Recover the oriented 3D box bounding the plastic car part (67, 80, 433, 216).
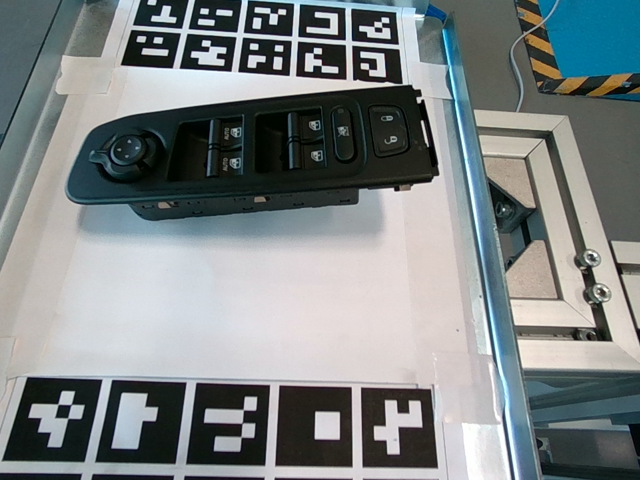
[{"bbox_3d":[-0.043,-0.048,0.255,0.203,0.066,0.067,-3,-15,2],"label":"plastic car part"}]
